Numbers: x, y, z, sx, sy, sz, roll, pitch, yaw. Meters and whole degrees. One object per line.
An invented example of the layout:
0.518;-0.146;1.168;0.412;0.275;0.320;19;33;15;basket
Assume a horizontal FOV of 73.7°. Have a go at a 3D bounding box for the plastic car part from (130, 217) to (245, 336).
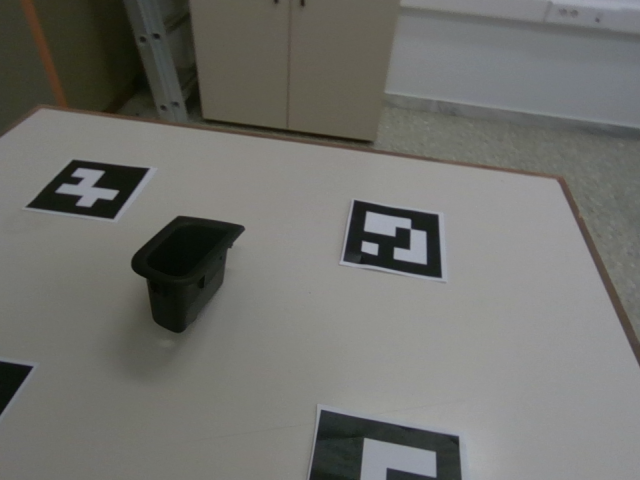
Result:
-0.110;0.033;0.352;0.066;0.071;0.116;8;26;5;plastic car part
